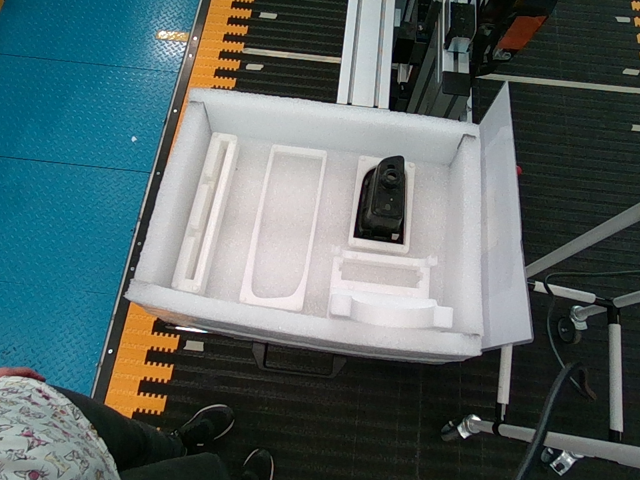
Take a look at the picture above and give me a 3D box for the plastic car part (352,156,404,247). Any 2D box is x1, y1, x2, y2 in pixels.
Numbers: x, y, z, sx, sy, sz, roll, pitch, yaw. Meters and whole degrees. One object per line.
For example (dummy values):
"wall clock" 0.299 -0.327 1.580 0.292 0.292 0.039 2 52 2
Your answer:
"plastic car part" 0.084 -0.059 0.547 0.066 0.116 0.071 9 -17 0
